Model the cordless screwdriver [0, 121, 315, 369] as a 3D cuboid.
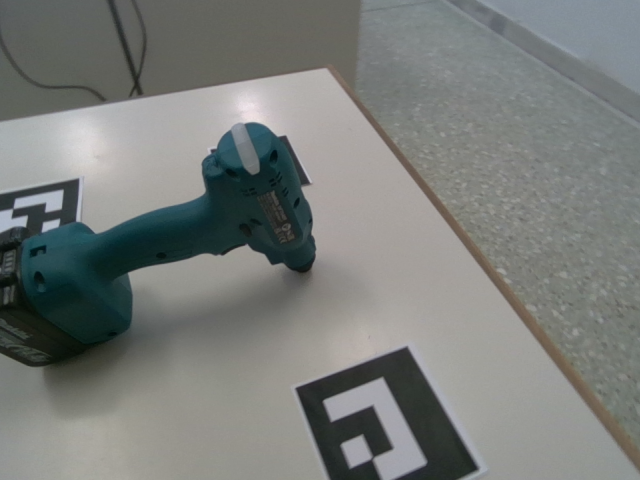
[{"bbox_3d":[-0.124,0.019,0.344,0.248,0.075,0.158,-24,-37,-2],"label":"cordless screwdriver"}]
